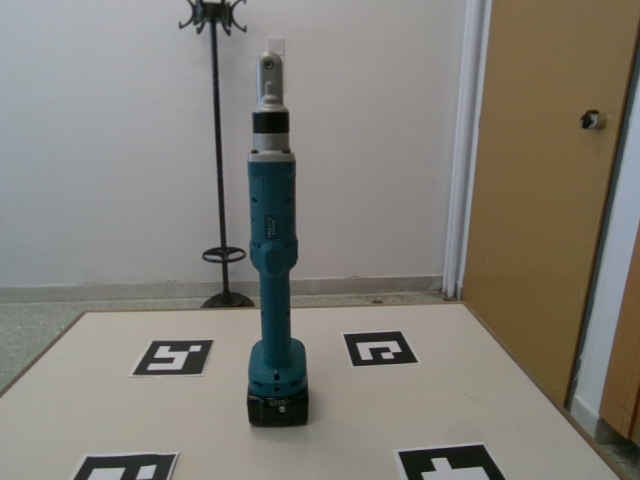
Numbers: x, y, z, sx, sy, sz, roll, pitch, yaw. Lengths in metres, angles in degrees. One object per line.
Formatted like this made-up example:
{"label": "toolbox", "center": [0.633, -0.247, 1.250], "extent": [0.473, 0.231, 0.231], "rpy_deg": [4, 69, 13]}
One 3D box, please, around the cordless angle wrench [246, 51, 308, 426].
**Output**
{"label": "cordless angle wrench", "center": [-0.054, 0.012, 0.493], "extent": [0.074, 0.423, 0.098], "rpy_deg": [-1, 16, -4]}
